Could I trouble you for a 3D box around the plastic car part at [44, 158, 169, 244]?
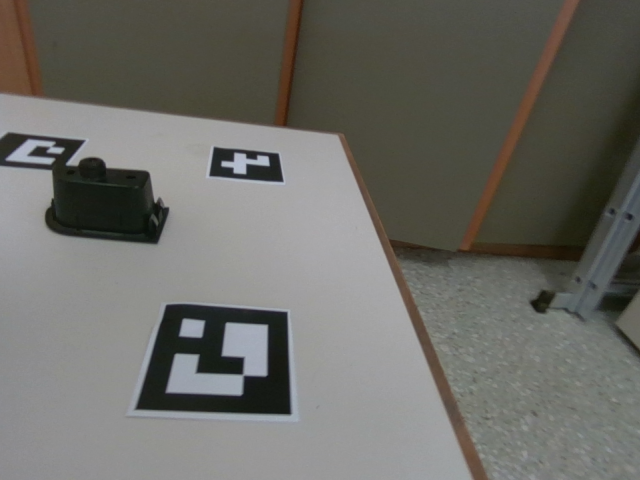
[{"bbox_3d":[-0.215,-0.044,0.423,0.116,0.071,0.066,7,31,-11],"label":"plastic car part"}]
